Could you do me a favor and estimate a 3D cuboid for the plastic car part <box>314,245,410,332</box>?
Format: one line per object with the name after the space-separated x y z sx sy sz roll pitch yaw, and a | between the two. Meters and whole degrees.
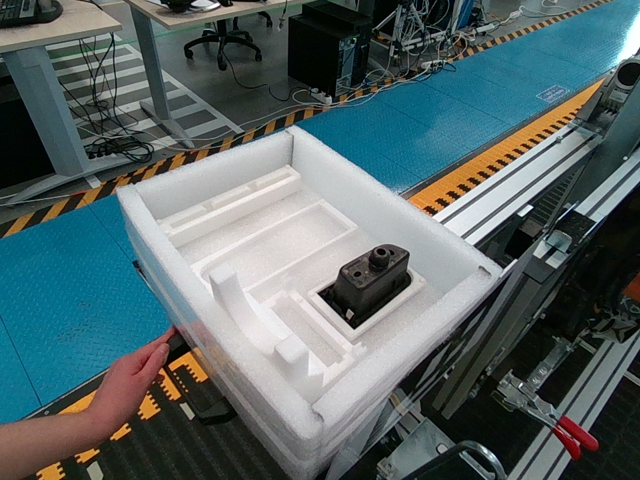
0.060 0.042 0.503 0.116 0.071 0.066 -30 56 -27 | plastic car part
